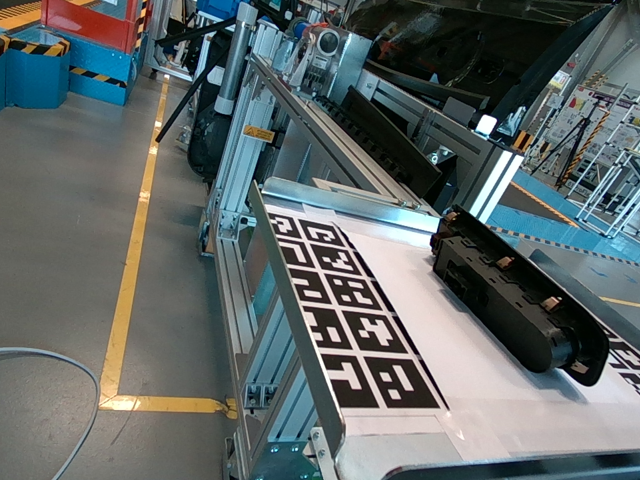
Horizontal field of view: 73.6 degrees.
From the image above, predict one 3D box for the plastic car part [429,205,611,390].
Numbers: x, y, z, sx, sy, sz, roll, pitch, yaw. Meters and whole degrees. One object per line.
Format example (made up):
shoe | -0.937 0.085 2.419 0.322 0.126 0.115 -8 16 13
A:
plastic car part | 0.158 0.043 0.382 0.067 0.066 0.203 -5 35 -26
